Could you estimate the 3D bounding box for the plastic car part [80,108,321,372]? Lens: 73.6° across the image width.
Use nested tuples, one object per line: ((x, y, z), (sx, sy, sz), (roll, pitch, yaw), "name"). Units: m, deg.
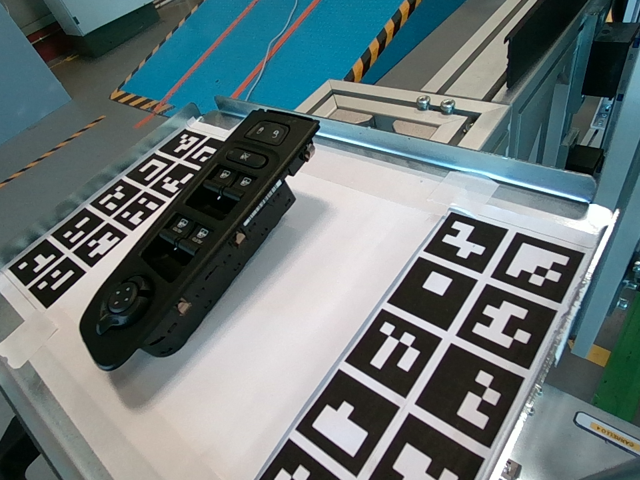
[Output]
((-0.075, -0.002, 0.292), (0.066, 0.202, 0.067), (26, -24, 27), "plastic car part")
